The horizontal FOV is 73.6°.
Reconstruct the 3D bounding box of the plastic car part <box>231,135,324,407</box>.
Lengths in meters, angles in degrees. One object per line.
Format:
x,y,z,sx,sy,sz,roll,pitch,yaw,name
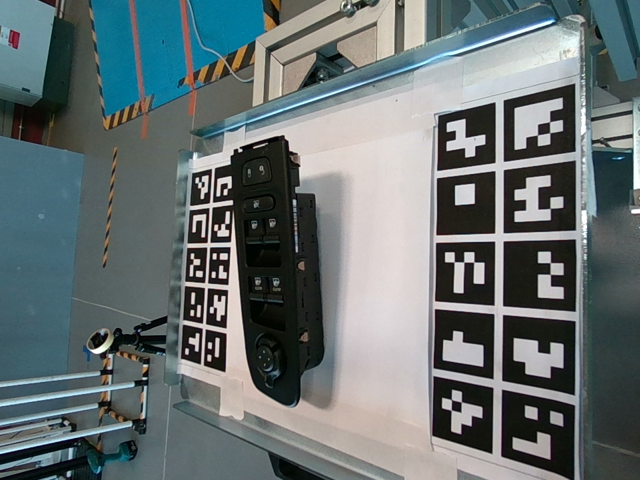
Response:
-0.031,0.026,0.346,0.067,0.202,0.066,-2,-2,34,plastic car part
